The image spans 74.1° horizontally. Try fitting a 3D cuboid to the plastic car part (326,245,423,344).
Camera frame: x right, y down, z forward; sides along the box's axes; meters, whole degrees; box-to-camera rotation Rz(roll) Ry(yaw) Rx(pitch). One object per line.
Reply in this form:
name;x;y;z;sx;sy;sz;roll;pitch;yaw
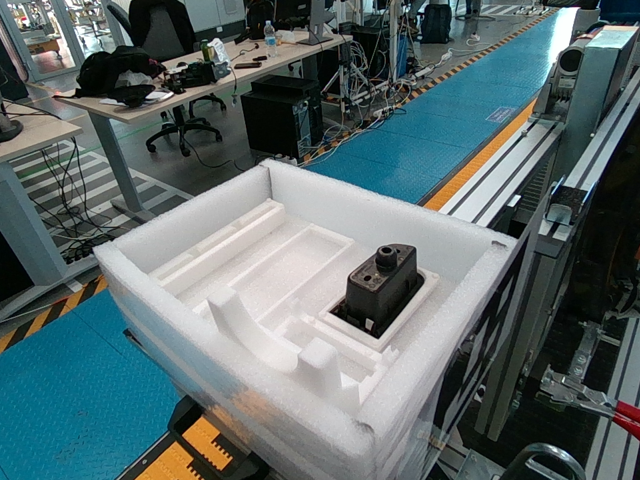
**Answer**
plastic car part;0.067;0.043;0.464;0.066;0.071;0.116;24;48;34
